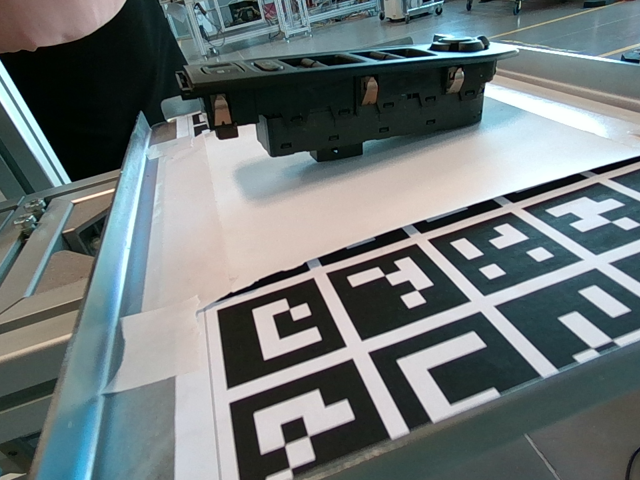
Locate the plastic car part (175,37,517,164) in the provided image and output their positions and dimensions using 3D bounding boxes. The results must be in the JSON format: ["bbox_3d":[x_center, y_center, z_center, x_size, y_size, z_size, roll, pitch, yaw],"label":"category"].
[{"bbox_3d":[0.025,-0.085,0.253,0.202,0.067,0.066,-16,25,-13],"label":"plastic car part"}]
